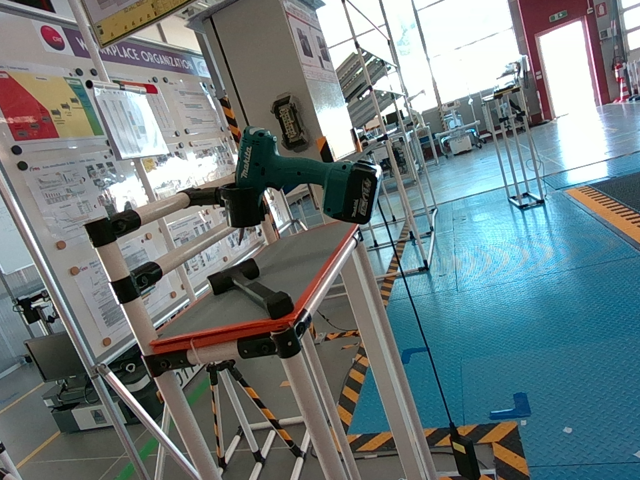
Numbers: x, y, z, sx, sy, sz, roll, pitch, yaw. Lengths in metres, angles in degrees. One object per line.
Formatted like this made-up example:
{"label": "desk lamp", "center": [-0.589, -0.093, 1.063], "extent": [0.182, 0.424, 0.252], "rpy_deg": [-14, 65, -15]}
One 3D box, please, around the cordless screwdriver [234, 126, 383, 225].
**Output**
{"label": "cordless screwdriver", "center": [-0.028, -0.082, 0.707], "extent": [0.249, 0.159, 0.074], "rpy_deg": [17, 20, 10]}
